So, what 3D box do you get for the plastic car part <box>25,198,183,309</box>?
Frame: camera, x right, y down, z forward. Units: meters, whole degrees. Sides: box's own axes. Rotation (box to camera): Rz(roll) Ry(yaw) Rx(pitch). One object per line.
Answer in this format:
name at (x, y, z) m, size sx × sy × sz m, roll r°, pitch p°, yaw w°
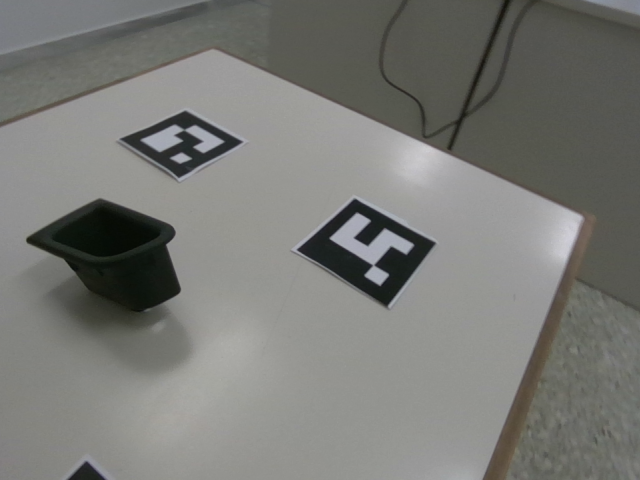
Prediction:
plastic car part at (-0.149, 0.018, 0.321) m, size 0.117 × 0.071 × 0.065 m, roll 17°, pitch 45°, yaw 32°
